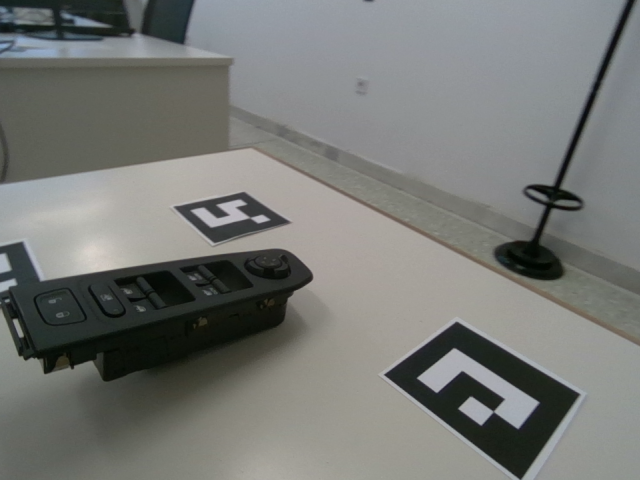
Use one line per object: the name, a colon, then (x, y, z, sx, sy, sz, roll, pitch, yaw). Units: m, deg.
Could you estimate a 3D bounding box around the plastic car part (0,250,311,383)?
plastic car part: (-0.089, 0.049, 0.295, 0.201, 0.067, 0.067, -15, 27, -41)
